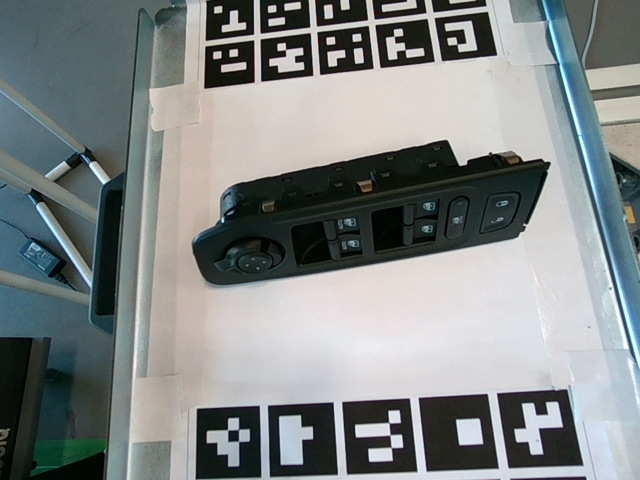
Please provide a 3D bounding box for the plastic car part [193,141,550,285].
[{"bbox_3d":[0.021,-0.020,0.260,0.203,0.067,0.066,-14,-29,0],"label":"plastic car part"}]
